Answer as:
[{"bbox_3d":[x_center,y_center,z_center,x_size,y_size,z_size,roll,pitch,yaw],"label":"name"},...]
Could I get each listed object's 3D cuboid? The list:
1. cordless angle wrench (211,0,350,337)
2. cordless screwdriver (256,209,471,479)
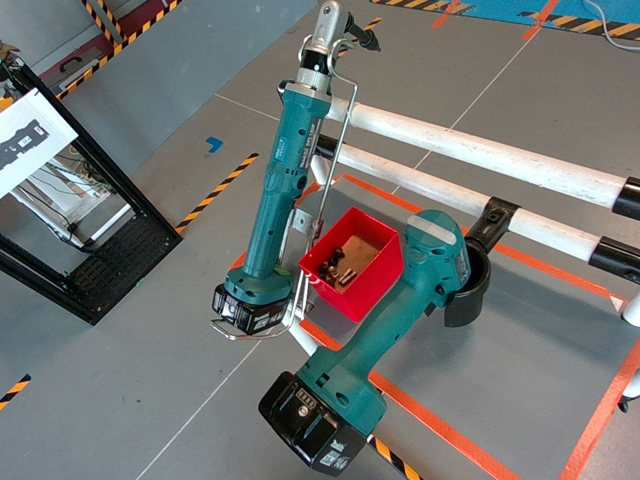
[{"bbox_3d":[-0.042,-0.080,0.545,0.074,0.423,0.098,26,18,29],"label":"cordless angle wrench"},{"bbox_3d":[0.063,0.103,0.415,0.074,0.248,0.159,32,-12,35],"label":"cordless screwdriver"}]
